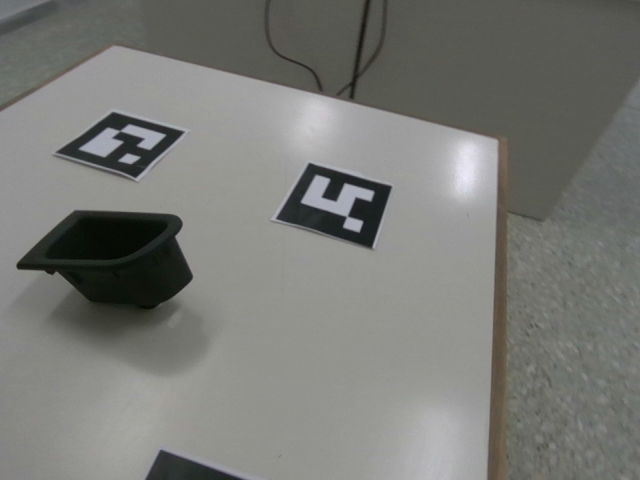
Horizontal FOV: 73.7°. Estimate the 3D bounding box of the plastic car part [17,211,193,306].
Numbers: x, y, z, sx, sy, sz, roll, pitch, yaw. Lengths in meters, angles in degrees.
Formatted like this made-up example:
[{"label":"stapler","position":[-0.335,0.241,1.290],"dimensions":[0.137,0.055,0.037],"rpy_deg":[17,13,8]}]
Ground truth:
[{"label":"plastic car part","position":[-0.149,0.021,0.325],"dimensions":[0.117,0.071,0.066],"rpy_deg":[3,46,20]}]
